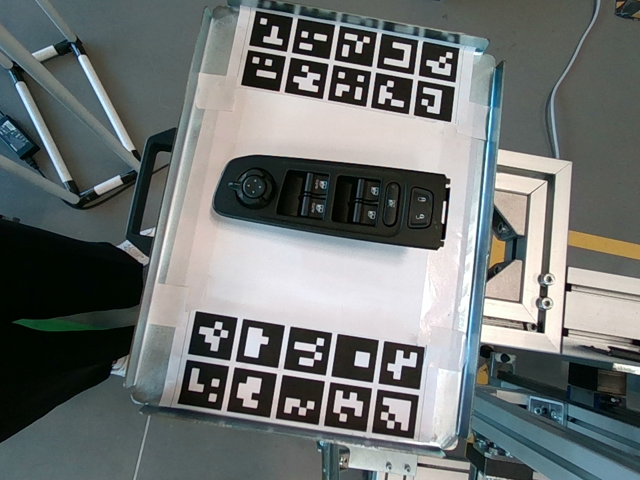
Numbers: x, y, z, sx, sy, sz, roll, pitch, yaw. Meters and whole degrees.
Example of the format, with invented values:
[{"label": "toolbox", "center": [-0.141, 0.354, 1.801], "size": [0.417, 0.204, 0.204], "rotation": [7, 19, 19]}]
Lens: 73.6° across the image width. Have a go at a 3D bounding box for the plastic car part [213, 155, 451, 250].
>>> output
[{"label": "plastic car part", "center": [0.008, -0.036, 0.388], "size": [0.203, 0.066, 0.067], "rotation": [8, -1, 1]}]
